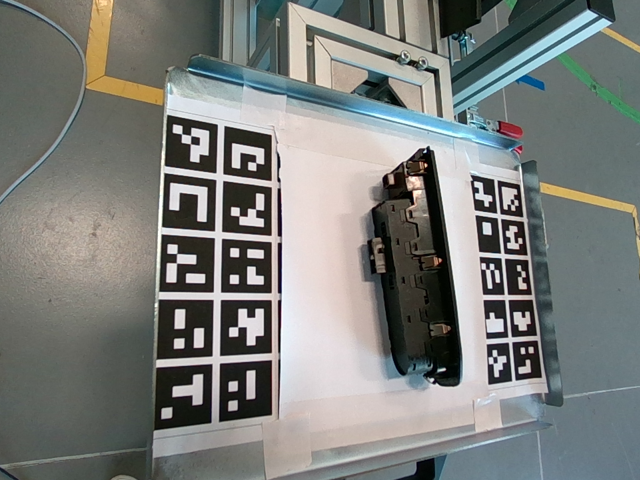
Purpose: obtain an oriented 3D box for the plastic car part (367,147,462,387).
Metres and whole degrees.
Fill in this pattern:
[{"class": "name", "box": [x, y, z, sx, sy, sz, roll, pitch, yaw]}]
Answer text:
[{"class": "plastic car part", "box": [0.079, 0.029, 0.365, 0.067, 0.203, 0.066, -9, -5, -18]}]
